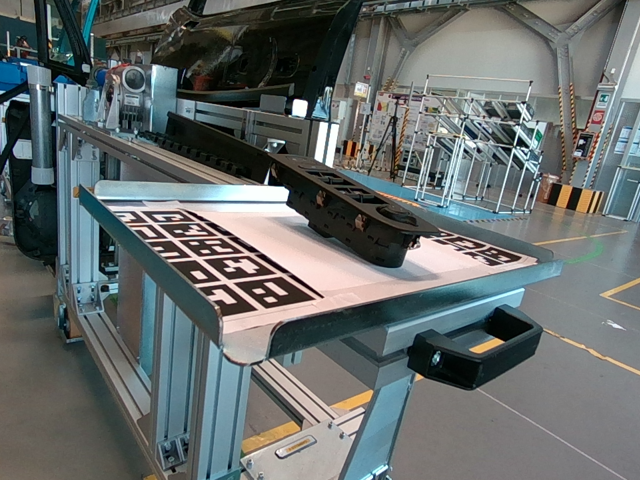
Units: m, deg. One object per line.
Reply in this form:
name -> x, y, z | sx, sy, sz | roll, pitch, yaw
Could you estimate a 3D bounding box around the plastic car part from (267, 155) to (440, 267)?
plastic car part -> 0.020, -0.031, 0.423 | 0.066, 0.067, 0.204 | 6, 18, -45
